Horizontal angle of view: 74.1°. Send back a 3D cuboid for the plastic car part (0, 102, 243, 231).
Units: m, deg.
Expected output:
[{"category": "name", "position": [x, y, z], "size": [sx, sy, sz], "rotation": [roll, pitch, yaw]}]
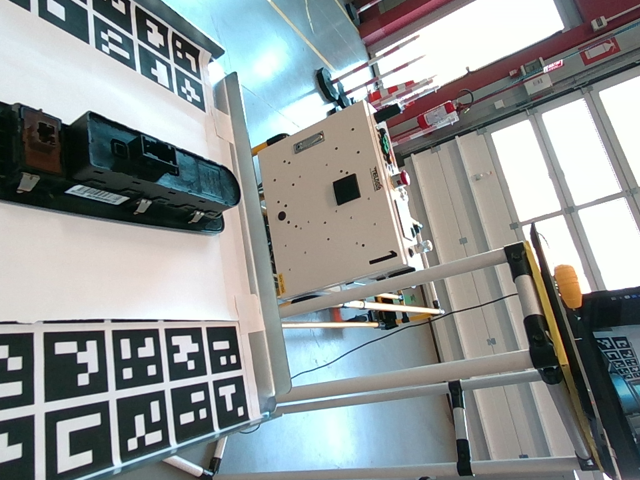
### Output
[{"category": "plastic car part", "position": [-0.132, -0.052, 0.331], "size": [0.067, 0.066, 0.202], "rotation": [-25, -19, 22]}]
